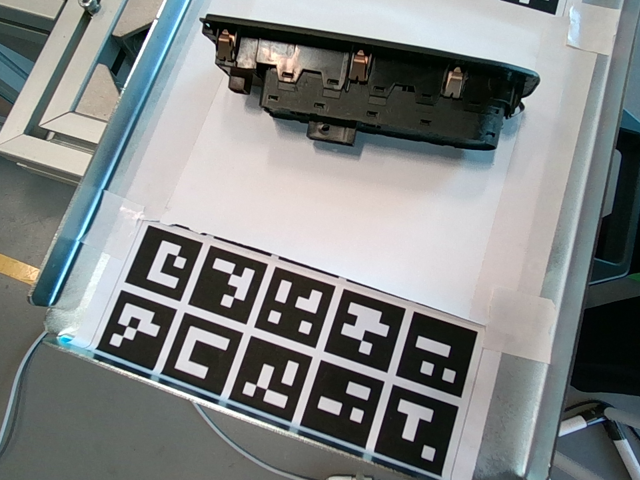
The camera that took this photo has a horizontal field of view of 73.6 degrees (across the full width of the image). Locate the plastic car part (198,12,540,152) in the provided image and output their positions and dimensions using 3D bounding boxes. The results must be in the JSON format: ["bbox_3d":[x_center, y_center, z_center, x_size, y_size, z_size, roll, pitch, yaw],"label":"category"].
[{"bbox_3d":[0.029,-0.091,0.264,0.203,0.067,0.066,7,-4,4],"label":"plastic car part"}]
